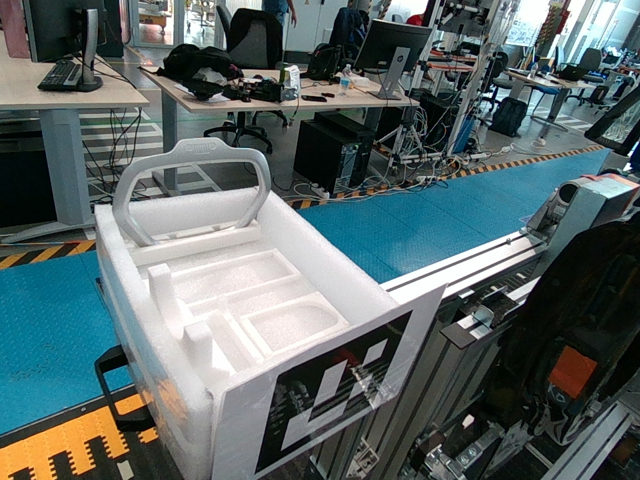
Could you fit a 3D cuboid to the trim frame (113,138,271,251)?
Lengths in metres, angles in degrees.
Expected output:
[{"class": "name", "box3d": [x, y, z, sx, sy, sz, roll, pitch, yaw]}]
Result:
[{"class": "trim frame", "box3d": [-0.184, -0.066, 0.647, 0.247, 0.185, 0.027, -14, 46, -32]}]
